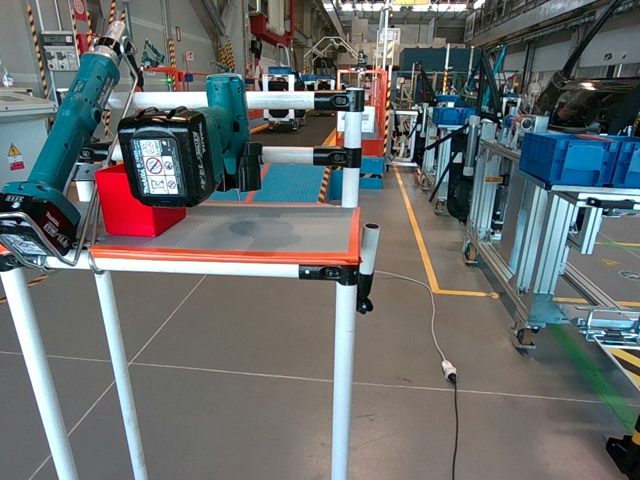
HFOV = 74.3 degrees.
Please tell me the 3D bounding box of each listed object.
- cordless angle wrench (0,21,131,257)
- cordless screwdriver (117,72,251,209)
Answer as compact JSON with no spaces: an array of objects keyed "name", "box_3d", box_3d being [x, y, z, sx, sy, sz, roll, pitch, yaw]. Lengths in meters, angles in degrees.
[{"name":"cordless angle wrench","box_3d":[-0.357,-0.182,0.629,0.074,0.421,0.098,6,-27,-1]},{"name":"cordless screwdriver","box_3d":[-0.137,-0.105,0.517,0.074,0.159,0.248,1,29,7]}]
